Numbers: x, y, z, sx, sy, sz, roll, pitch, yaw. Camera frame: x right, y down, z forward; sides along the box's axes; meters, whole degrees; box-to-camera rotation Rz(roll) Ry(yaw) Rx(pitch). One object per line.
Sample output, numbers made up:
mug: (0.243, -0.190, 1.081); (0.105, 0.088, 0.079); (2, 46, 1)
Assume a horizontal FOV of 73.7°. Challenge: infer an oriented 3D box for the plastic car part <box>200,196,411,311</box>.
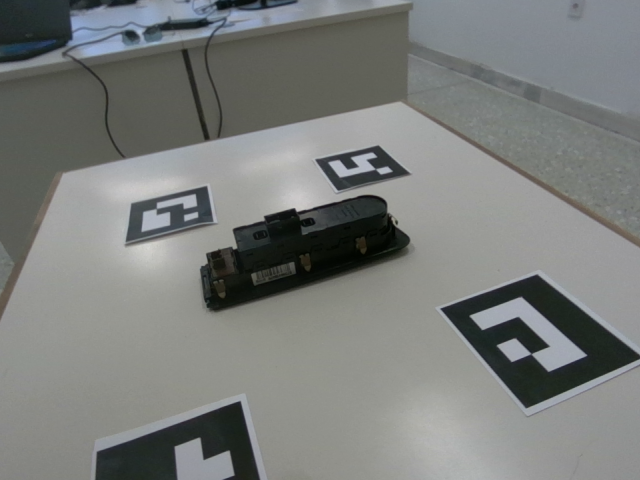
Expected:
plastic car part: (-0.015, 0.001, 0.407); (0.202, 0.067, 0.067); (-12, 26, -12)
